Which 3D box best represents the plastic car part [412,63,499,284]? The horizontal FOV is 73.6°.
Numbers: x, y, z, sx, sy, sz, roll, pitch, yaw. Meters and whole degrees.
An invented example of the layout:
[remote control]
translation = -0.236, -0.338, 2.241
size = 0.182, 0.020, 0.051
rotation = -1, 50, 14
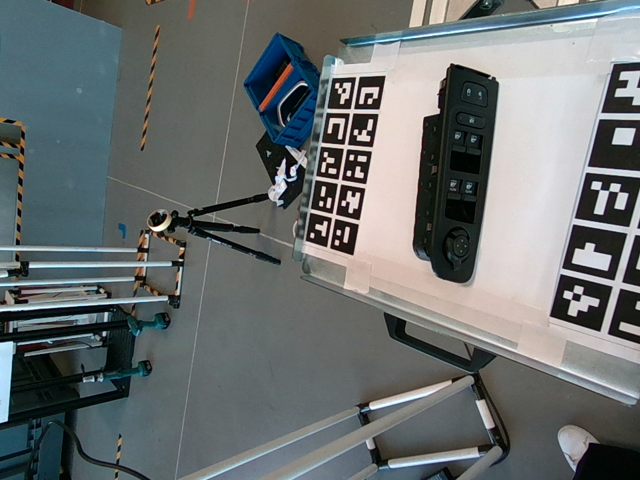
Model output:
[plastic car part]
translation = 0.124, -0.059, 0.421
size = 0.066, 0.203, 0.067
rotation = 3, -1, -35
